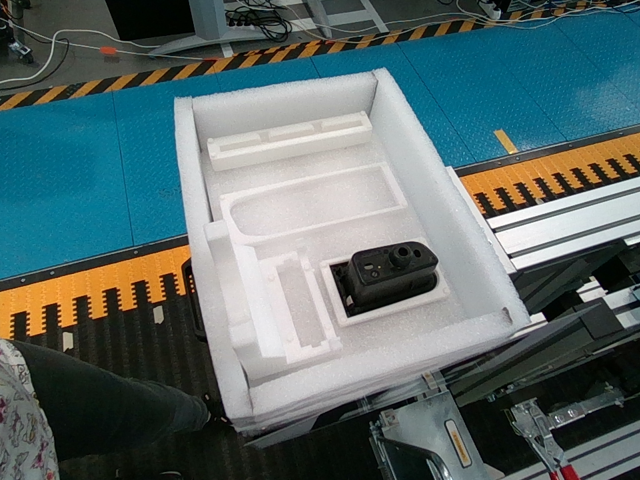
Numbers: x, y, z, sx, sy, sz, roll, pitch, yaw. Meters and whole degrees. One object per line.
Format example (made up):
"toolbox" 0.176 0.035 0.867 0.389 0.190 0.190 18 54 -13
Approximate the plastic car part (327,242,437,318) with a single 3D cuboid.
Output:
"plastic car part" 0.074 0.032 0.463 0.116 0.066 0.071 -14 -28 -9
